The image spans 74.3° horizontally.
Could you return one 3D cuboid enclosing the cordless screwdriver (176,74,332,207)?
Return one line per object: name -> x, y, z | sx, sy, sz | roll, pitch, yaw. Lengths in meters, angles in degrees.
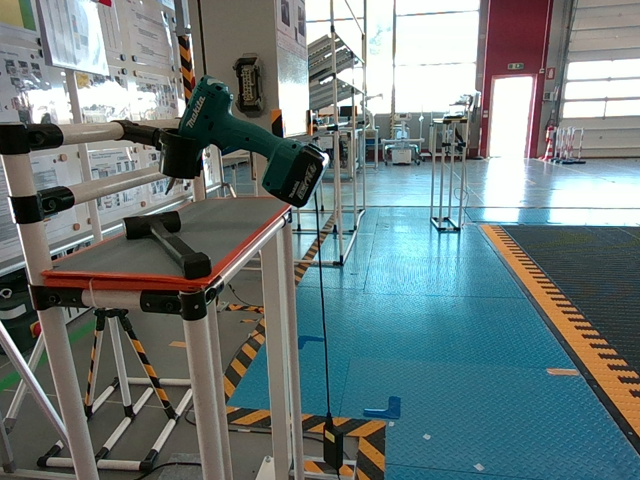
cordless screwdriver -> -0.116, -0.136, 0.692 | 0.249, 0.159, 0.074 | 32, 25, 0
